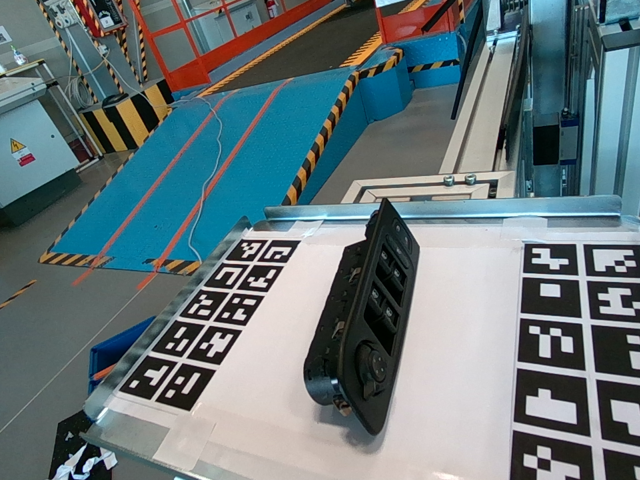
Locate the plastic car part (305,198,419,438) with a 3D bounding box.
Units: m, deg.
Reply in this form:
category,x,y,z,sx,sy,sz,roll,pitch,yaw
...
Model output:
category,x,y,z,sx,sy,sz,roll,pitch,yaw
plastic car part,0.033,0.049,0.335,0.067,0.066,0.202,-17,31,25
